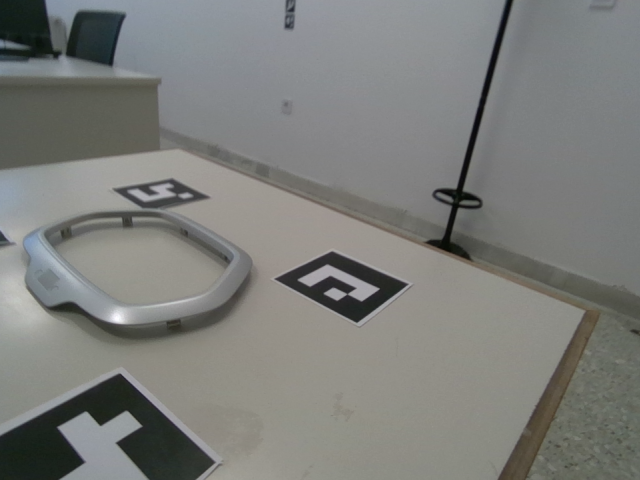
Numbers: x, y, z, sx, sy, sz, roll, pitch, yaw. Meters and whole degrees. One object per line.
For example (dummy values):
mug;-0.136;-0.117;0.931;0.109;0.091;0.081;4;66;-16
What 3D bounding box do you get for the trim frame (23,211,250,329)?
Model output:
trim frame;-0.184;0.018;0.427;0.251;0.027;0.182;27;30;33
